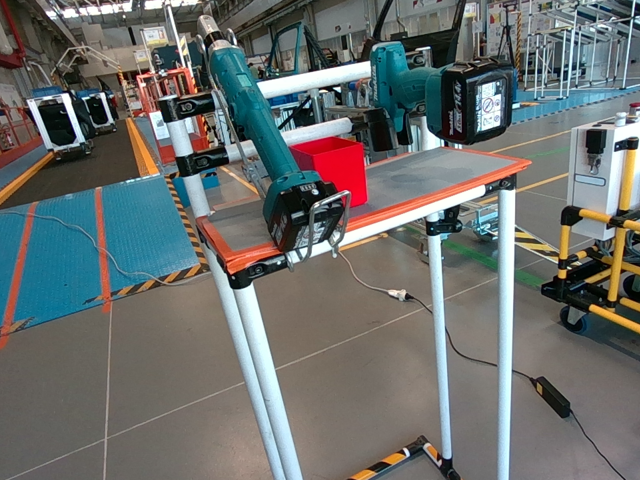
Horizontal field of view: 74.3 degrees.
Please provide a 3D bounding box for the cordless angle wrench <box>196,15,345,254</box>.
[{"bbox_3d":[-0.098,-0.179,0.594,0.074,0.422,0.098,-15,-26,-26],"label":"cordless angle wrench"}]

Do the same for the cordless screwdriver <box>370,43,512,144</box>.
[{"bbox_3d":[0.155,-0.193,0.613,0.074,0.159,0.248,-19,33,-17],"label":"cordless screwdriver"}]
